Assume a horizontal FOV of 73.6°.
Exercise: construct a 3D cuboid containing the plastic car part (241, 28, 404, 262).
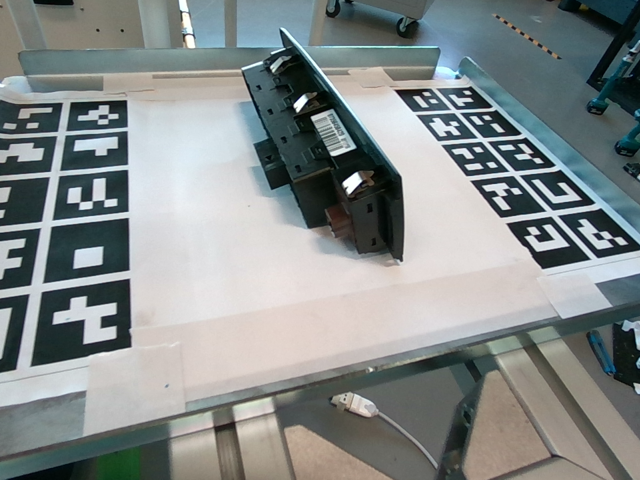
[{"bbox_3d":[-0.010,-0.069,0.280,0.067,0.203,0.066,-23,-39,4],"label":"plastic car part"}]
